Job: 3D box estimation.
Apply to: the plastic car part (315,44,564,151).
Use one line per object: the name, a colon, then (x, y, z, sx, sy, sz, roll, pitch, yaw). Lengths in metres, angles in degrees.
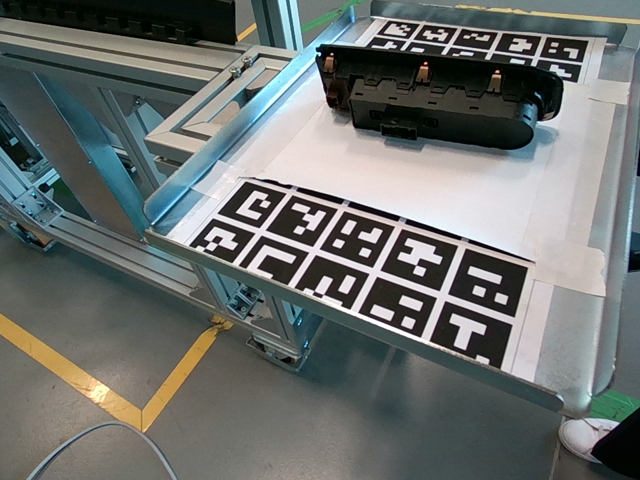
plastic car part: (0.090, -0.115, 0.353, 0.204, 0.067, 0.066, 10, -30, 16)
